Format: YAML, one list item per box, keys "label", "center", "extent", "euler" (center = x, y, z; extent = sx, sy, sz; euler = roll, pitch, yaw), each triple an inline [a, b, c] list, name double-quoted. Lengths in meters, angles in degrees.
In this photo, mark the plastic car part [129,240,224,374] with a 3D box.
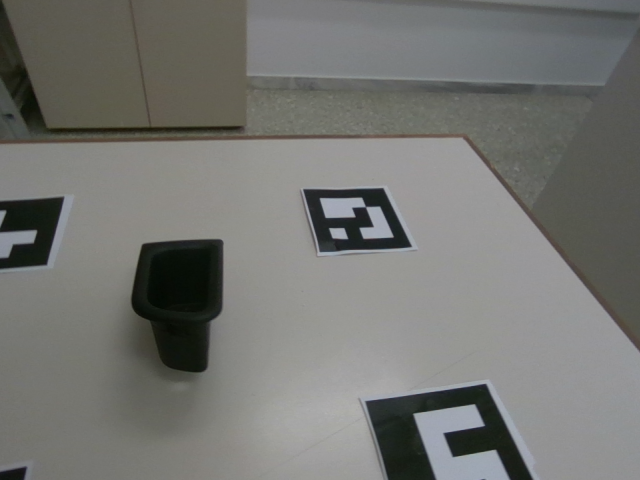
- label: "plastic car part"
  center: [-0.104, 0.054, 0.321]
  extent: [0.066, 0.071, 0.117]
  euler: [-3, 29, -12]
